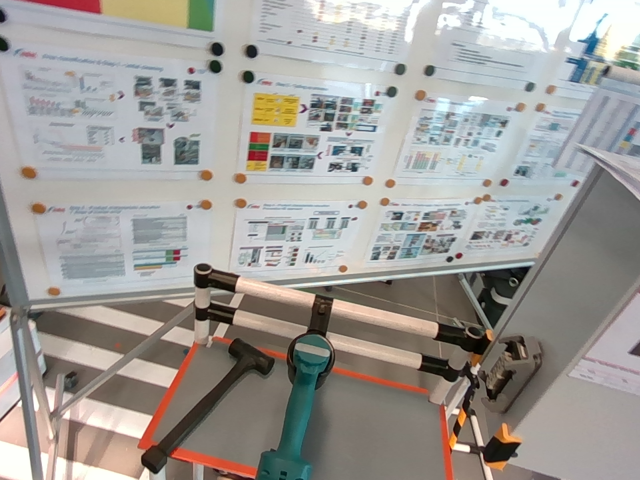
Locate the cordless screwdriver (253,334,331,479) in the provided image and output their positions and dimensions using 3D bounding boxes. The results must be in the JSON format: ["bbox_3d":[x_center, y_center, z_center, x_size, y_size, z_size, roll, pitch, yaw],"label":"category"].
[{"bbox_3d":[-0.036,0.269,0.612,0.074,0.248,0.159,13,-23,4],"label":"cordless screwdriver"}]
